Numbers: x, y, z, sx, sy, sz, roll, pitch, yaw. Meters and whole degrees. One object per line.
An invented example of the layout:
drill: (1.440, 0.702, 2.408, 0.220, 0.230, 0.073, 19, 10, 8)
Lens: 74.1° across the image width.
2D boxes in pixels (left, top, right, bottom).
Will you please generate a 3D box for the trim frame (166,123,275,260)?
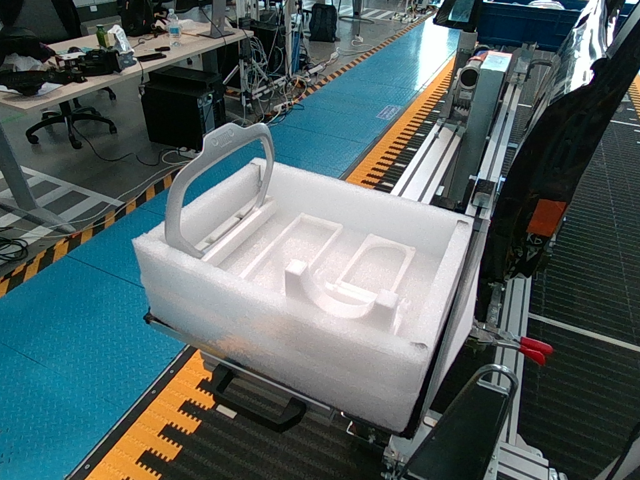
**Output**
trim frame: (-0.136, -0.074, 0.620, 0.027, 0.184, 0.247, 25, 45, 19)
